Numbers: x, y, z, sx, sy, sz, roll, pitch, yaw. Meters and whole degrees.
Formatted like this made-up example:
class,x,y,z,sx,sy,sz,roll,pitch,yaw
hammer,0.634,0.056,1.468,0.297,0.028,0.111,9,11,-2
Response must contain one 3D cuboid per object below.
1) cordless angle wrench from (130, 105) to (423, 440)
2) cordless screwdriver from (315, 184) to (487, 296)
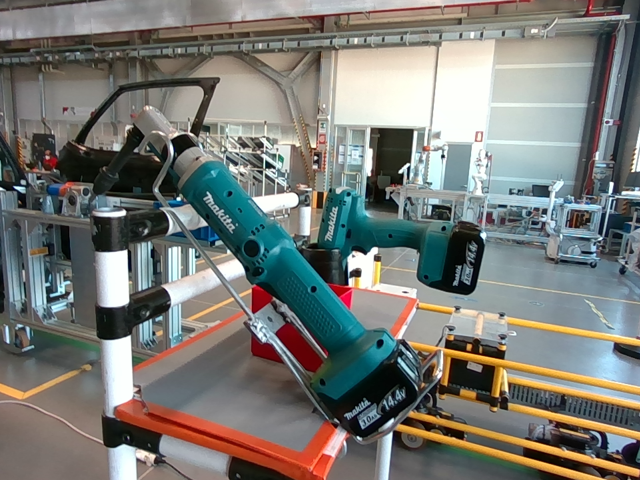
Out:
class,x,y,z,sx,sy,sz,roll,pitch,yaw
cordless angle wrench,-0.063,0.010,0.452,0.098,0.423,0.074,-43,-7,14
cordless screwdriver,0.109,0.022,0.630,0.249,0.159,0.074,17,15,20
